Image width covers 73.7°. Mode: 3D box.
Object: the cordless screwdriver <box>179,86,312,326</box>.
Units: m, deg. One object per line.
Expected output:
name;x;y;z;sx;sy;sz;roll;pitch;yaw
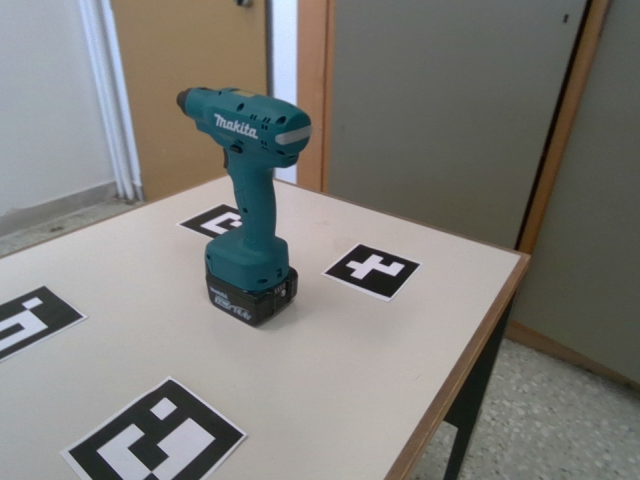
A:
cordless screwdriver;-0.092;-0.038;0.473;0.160;0.249;0.073;25;36;29
